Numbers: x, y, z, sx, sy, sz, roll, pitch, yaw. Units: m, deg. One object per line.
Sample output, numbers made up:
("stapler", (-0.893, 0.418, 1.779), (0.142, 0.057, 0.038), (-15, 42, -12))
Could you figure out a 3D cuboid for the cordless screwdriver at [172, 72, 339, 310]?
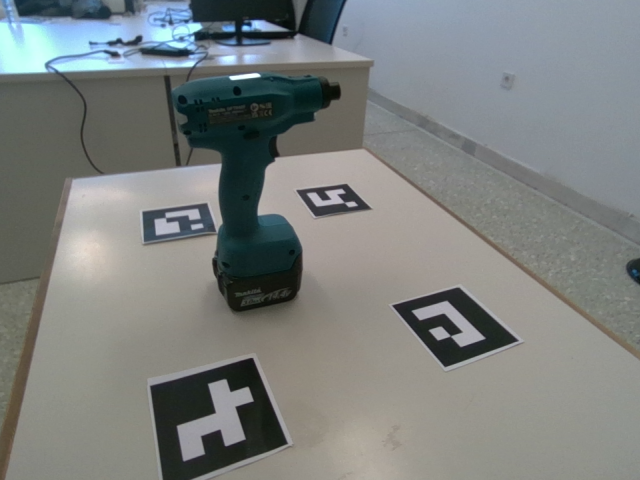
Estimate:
("cordless screwdriver", (-0.054, -0.049, 0.460), (0.158, 0.248, 0.075), (-13, 35, -16))
